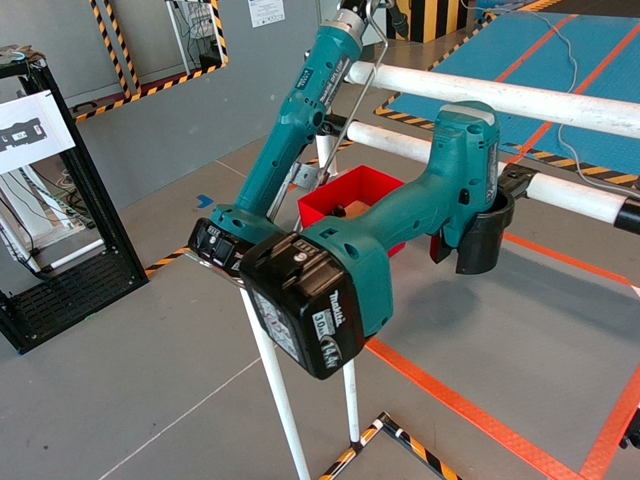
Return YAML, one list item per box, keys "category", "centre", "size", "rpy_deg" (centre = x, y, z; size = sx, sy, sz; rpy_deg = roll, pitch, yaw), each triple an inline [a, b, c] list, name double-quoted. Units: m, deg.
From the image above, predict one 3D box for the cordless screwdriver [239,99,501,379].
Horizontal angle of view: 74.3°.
- category: "cordless screwdriver"
  centre: [0.064, 0.009, 0.356]
  size: [0.248, 0.159, 0.074]
  rpy_deg: [-38, 45, -22]

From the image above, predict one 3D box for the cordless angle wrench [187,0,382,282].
- category: "cordless angle wrench"
  centre: [-0.022, -0.153, 0.523]
  size: [0.074, 0.423, 0.098]
  rpy_deg: [29, 2, 30]
